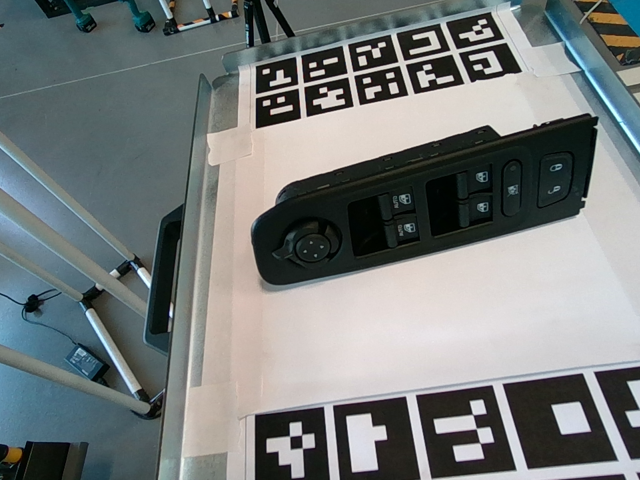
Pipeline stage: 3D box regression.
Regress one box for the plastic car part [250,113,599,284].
[{"bbox_3d":[0.052,-0.029,0.263,0.203,0.067,0.066,-18,-45,1],"label":"plastic car part"}]
